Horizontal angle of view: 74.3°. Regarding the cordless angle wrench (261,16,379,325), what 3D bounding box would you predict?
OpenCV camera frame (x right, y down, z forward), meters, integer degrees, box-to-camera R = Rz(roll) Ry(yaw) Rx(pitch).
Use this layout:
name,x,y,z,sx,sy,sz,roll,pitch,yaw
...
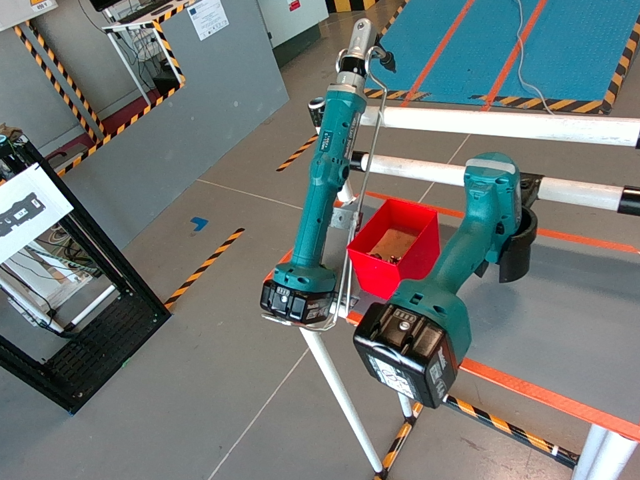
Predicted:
name,x,y,z,sx,sy,sz,roll,pitch,yaw
cordless angle wrench,0.015,-0.096,0.589,0.074,0.423,0.098,17,6,32

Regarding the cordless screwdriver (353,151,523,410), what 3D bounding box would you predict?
name,x,y,z,sx,sy,sz,roll,pitch,yaw
cordless screwdriver,0.142,0.047,0.436,0.074,0.248,0.159,18,-28,38
